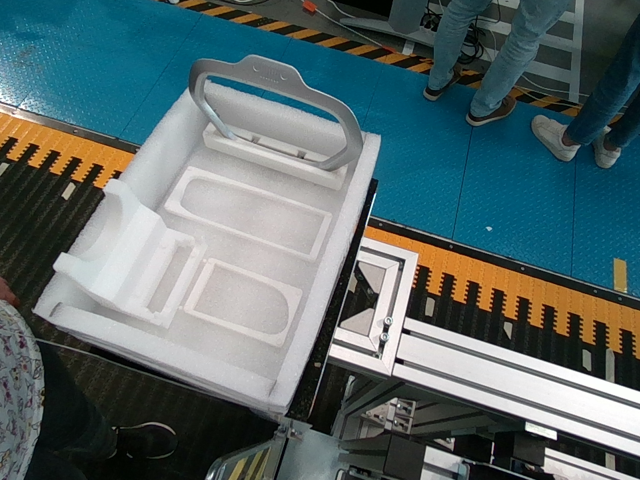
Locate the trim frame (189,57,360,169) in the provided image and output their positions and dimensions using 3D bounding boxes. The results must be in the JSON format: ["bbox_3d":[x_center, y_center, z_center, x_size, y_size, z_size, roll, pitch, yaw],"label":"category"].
[{"bbox_3d":[-0.064,-0.167,0.582,0.249,0.027,0.184,20,-22,6],"label":"trim frame"}]
